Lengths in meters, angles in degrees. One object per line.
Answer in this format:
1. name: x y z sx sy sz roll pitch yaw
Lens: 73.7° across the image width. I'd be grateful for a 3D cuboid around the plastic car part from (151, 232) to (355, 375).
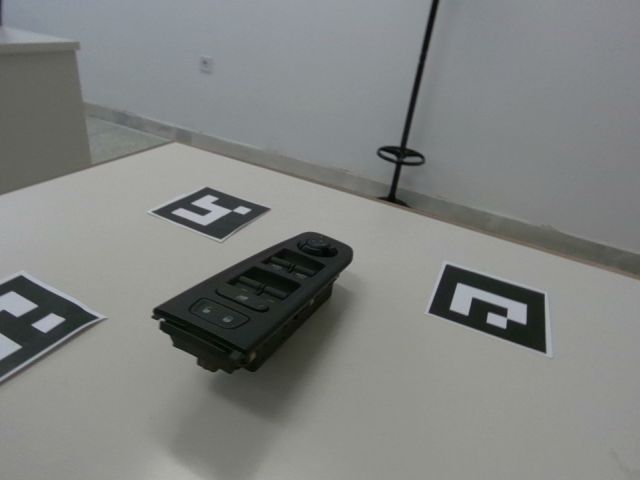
1. plastic car part: -0.029 0.044 0.328 0.067 0.067 0.201 11 25 23
